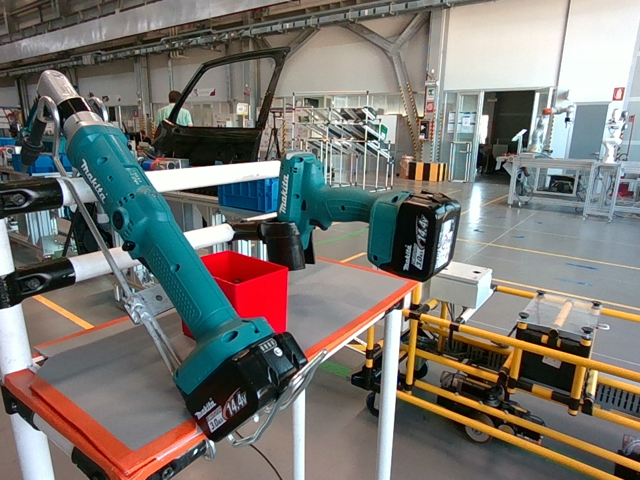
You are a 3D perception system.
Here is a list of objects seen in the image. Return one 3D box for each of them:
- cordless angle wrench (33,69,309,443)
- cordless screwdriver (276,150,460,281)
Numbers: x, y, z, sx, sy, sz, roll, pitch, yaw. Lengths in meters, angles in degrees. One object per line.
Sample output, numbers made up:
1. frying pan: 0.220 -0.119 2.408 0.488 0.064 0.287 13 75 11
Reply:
1. cordless angle wrench: -0.173 -0.018 0.411 0.098 0.422 0.074 -46 -16 29
2. cordless screwdriver: 0.041 -0.014 0.545 0.249 0.159 0.074 22 25 32
